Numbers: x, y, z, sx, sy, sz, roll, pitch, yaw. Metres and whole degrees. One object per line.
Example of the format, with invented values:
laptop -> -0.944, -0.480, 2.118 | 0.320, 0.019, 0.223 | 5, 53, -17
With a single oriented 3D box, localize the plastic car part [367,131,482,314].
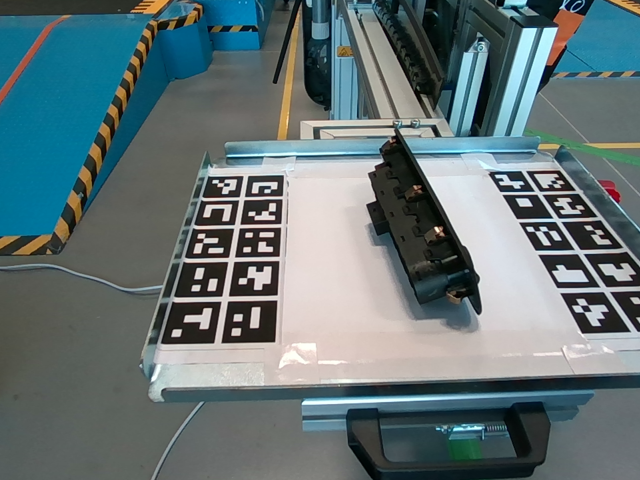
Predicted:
plastic car part -> 0.081, -0.019, 0.382 | 0.067, 0.066, 0.203 | -17, 43, -1
